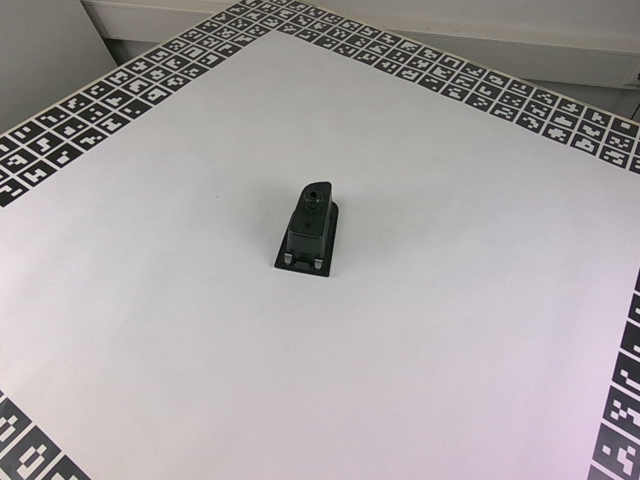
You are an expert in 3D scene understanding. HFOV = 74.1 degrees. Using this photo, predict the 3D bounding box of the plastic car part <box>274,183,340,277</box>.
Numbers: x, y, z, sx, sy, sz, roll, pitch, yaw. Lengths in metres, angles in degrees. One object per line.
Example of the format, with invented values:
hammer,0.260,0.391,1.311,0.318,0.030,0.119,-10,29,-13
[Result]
plastic car part,-0.010,-0.024,0.512,0.066,0.116,0.071,10,-33,7
